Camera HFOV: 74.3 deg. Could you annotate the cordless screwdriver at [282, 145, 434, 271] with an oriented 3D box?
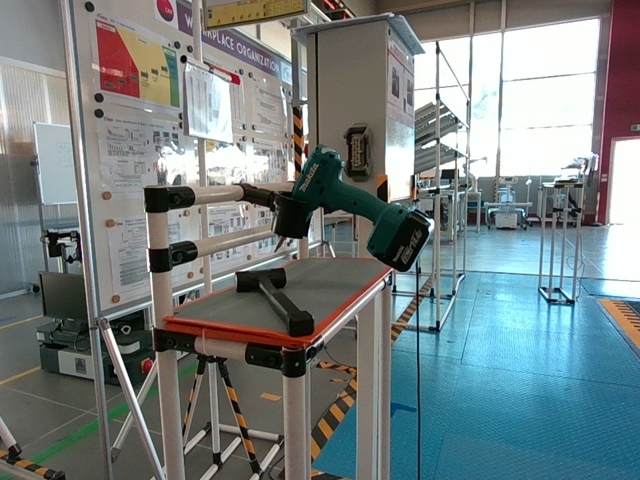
[{"bbox_3d":[0.058,-0.033,0.724,0.249,0.159,0.074,34,19,10],"label":"cordless screwdriver"}]
